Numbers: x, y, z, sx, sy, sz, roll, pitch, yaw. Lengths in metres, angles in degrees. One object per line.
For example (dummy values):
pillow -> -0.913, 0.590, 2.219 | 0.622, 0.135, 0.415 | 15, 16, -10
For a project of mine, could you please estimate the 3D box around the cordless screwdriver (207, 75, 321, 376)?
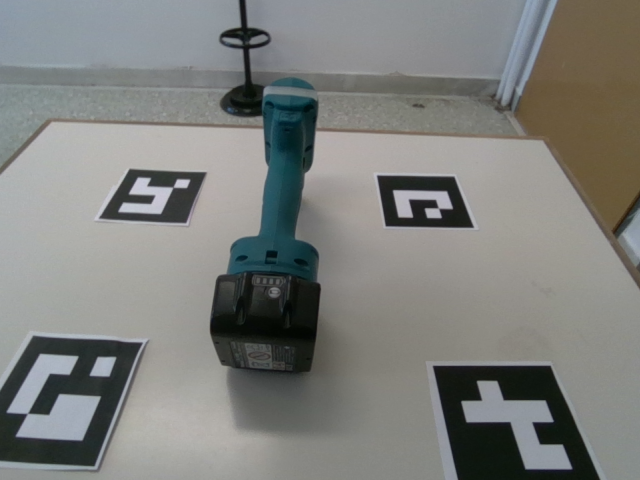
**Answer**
cordless screwdriver -> -0.037, -0.006, 0.387 | 0.074, 0.248, 0.159 | 5, -31, -2
